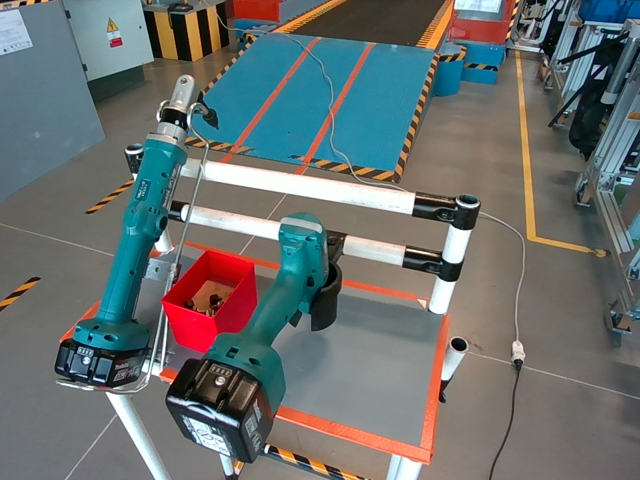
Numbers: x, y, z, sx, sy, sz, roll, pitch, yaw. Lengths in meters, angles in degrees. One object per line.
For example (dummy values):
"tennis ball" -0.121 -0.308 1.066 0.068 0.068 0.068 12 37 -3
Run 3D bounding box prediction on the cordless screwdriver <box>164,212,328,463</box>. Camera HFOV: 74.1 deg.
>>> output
"cordless screwdriver" -0.052 0.104 0.461 0.074 0.159 0.248 13 48 18

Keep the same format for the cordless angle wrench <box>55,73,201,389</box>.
"cordless angle wrench" -0.231 -0.027 0.567 0.074 0.422 0.098 12 -8 12
